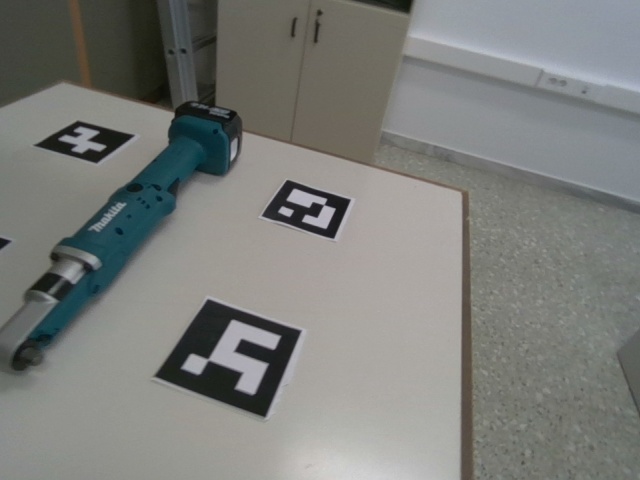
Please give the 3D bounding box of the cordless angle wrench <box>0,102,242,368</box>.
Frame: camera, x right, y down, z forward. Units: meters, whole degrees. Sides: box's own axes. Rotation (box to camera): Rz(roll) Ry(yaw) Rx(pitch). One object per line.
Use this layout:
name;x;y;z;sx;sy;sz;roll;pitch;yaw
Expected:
cordless angle wrench;-0.208;-0.038;0.493;0.098;0.074;0.421;15;42;5
